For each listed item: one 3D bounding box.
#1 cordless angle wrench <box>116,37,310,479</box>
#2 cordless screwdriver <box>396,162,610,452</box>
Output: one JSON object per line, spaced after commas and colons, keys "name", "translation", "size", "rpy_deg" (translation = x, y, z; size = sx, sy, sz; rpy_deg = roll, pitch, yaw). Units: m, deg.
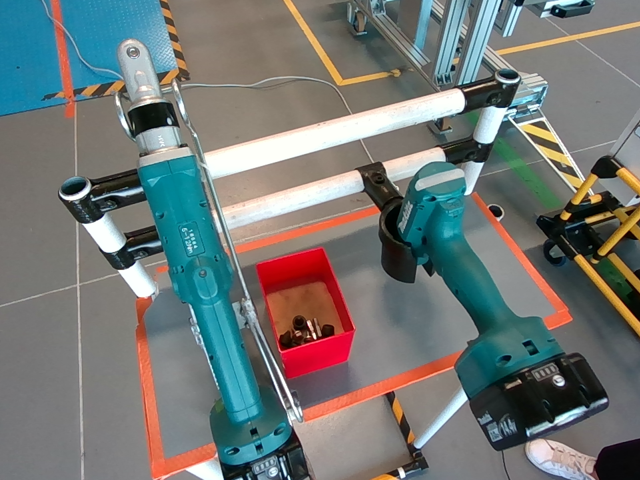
{"name": "cordless angle wrench", "translation": [-0.108, 0.031, 0.389], "size": [0.074, 0.423, 0.098], "rpy_deg": [-18, 8, -16]}
{"name": "cordless screwdriver", "translation": [0.142, 0.063, 0.411], "size": [0.074, 0.248, 0.159], "rpy_deg": [-17, -27, -9]}
